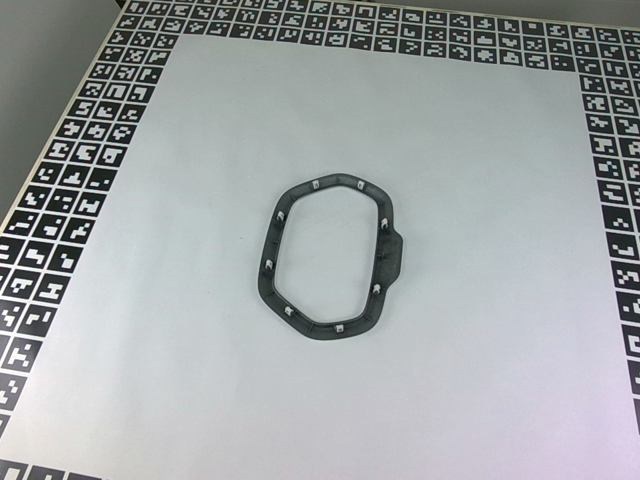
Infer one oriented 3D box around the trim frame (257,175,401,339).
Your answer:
[{"bbox_3d":[0.015,0.011,0.571,0.184,0.247,0.027,8,-30,5],"label":"trim frame"}]
